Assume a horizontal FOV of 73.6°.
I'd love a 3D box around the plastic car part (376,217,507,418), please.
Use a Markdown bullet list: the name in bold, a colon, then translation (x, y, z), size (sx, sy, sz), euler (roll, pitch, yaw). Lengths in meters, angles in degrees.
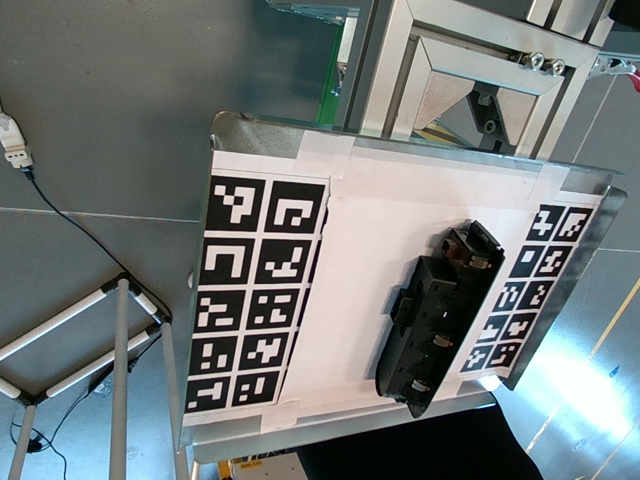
- **plastic car part**: translation (0.096, 0.080, 0.386), size (0.067, 0.203, 0.066), euler (3, 28, -13)
